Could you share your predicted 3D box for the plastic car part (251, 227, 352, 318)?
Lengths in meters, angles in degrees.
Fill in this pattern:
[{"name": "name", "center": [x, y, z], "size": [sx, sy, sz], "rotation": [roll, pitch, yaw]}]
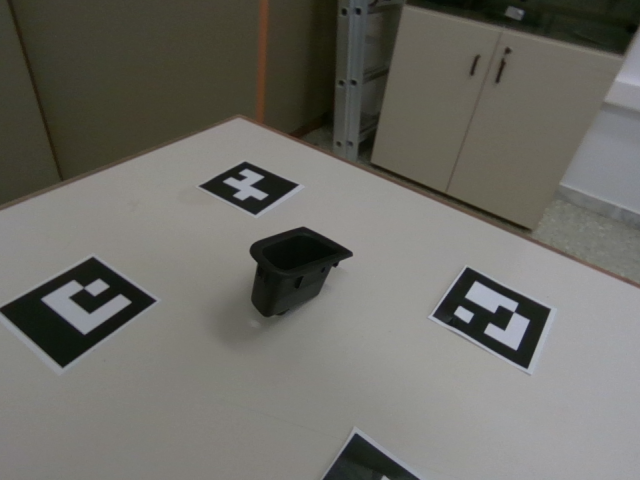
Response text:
[{"name": "plastic car part", "center": [-0.030, 0.038, 0.416], "size": [0.066, 0.071, 0.115], "rotation": [29, 27, 23]}]
